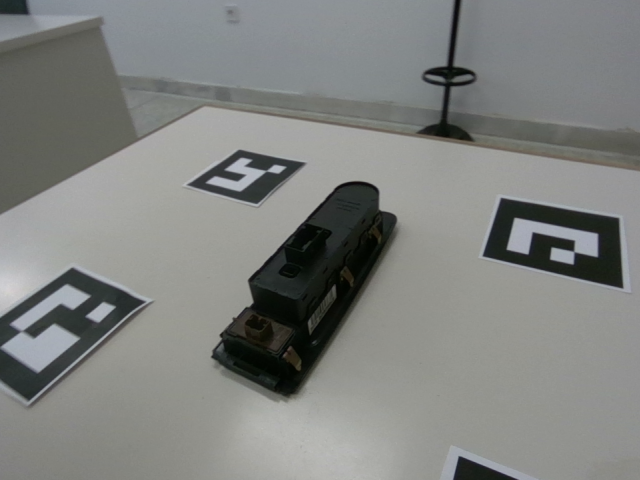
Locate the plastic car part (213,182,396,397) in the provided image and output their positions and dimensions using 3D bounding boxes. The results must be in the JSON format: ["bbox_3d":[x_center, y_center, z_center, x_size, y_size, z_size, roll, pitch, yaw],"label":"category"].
[{"bbox_3d":[-0.001,0.014,0.328,0.067,0.067,0.201,8,35,30],"label":"plastic car part"}]
